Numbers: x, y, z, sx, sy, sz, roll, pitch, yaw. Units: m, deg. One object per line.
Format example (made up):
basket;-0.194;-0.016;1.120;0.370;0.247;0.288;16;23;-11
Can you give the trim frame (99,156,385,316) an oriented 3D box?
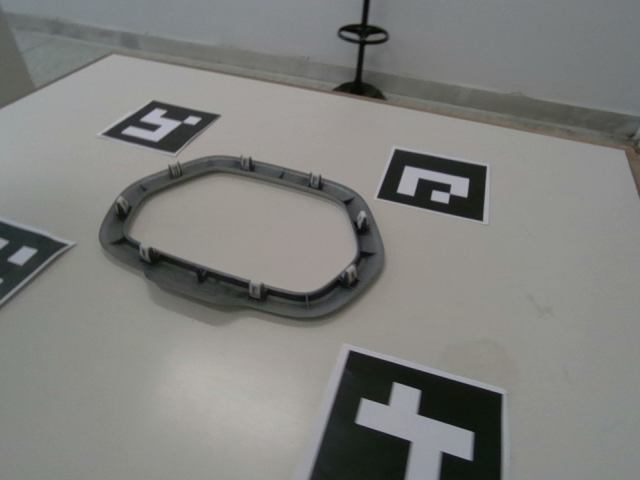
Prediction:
trim frame;-0.066;-0.017;0.369;0.250;0.027;0.183;17;46;14
